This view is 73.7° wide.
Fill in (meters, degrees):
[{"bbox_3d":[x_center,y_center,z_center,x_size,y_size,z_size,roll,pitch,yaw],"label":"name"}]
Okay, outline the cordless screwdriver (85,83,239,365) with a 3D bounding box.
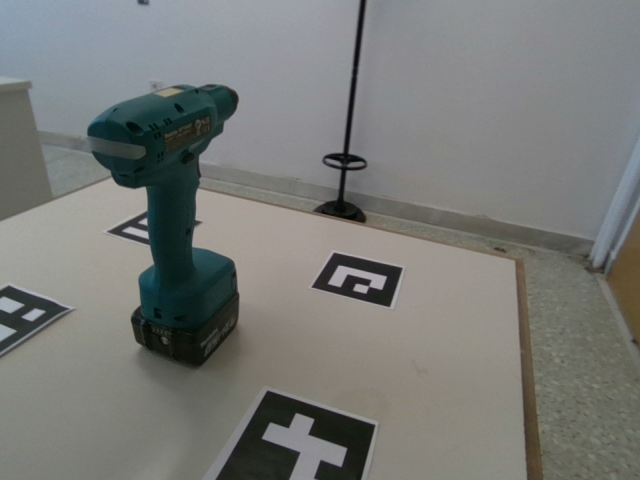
[{"bbox_3d":[-0.119,-0.016,0.404,0.075,0.249,0.158,14,34,16],"label":"cordless screwdriver"}]
